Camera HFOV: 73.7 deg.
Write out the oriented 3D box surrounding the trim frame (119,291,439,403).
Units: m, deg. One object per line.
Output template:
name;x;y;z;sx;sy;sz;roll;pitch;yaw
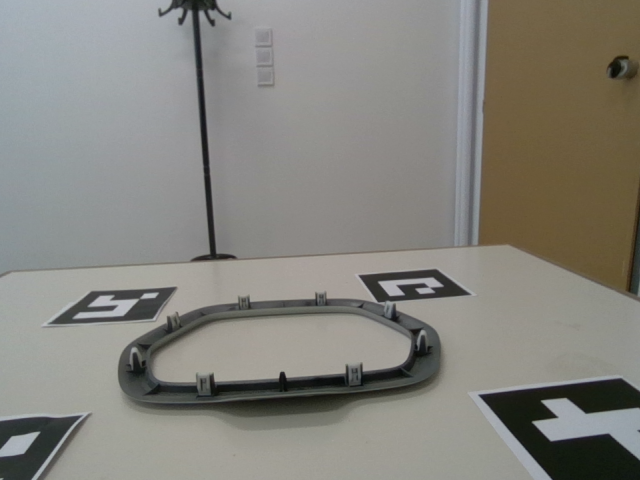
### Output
trim frame;-0.030;0.079;0.343;0.248;0.027;0.184;-1;14;-2
